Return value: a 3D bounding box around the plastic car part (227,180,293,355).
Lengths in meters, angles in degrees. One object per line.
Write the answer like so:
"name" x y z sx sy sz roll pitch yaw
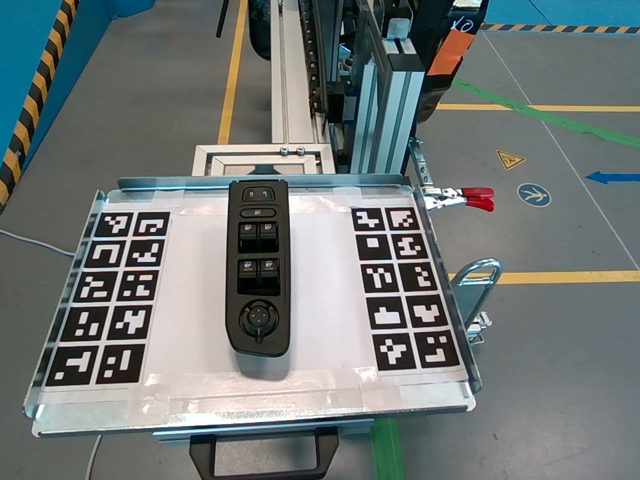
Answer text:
"plastic car part" -0.065 0.029 0.453 0.066 0.202 0.067 2 -36 -12
